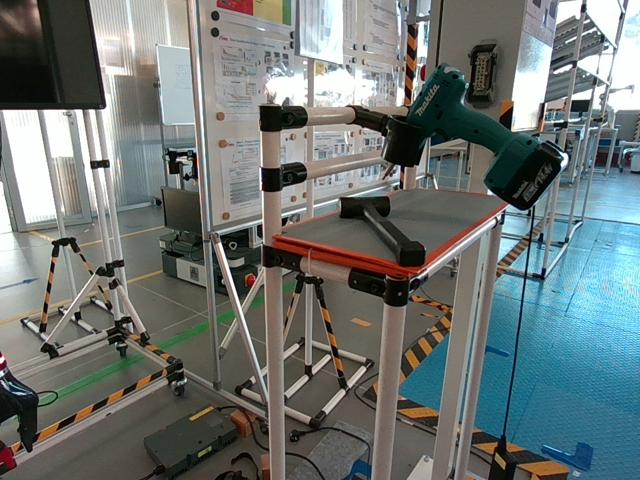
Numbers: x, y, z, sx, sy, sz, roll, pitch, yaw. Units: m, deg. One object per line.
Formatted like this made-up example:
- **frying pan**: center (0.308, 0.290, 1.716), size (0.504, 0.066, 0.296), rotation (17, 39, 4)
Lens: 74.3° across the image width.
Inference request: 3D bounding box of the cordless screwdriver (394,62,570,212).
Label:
- **cordless screwdriver**: center (0.235, -0.138, 0.654), size (0.248, 0.160, 0.074), rotation (45, 36, 18)
